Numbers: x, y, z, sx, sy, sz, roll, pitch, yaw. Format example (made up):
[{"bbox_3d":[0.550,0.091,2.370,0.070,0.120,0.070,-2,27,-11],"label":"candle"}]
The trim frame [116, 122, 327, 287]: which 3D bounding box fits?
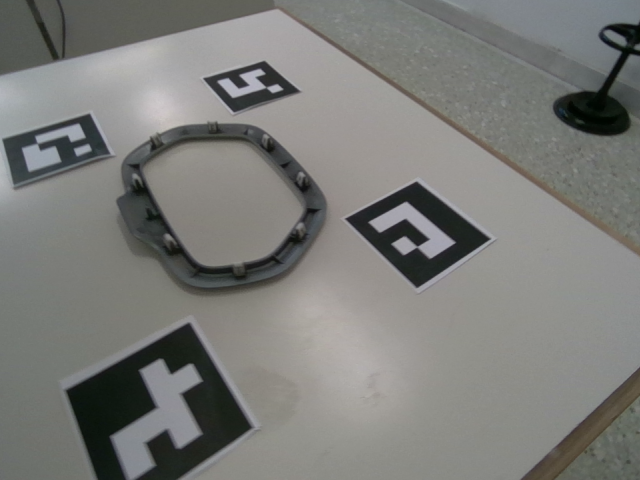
[{"bbox_3d":[-0.104,-0.052,0.431,0.183,0.250,0.027,-26,-34,-20],"label":"trim frame"}]
